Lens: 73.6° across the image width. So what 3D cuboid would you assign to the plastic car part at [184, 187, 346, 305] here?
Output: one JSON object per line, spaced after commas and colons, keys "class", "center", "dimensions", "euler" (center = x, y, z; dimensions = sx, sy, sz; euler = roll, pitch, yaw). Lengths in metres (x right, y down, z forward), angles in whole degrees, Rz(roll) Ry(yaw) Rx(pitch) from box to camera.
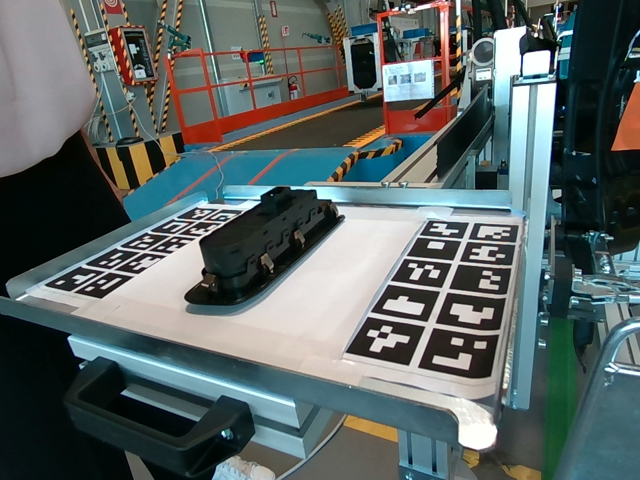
{"class": "plastic car part", "center": [-0.042, -0.007, 0.390], "dimensions": [0.067, 0.067, 0.201], "euler": [11, 31, 23]}
